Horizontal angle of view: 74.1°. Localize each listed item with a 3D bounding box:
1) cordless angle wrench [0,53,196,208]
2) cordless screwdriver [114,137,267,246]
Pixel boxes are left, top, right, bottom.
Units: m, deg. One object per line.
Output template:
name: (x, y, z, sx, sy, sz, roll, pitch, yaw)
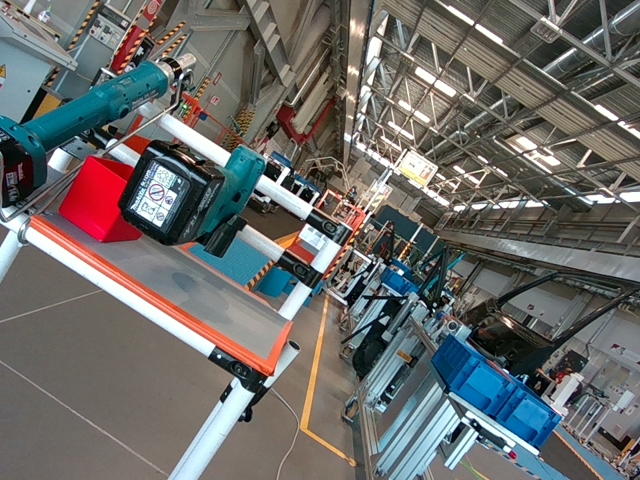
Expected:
cordless angle wrench: (-0.319, -0.205, 0.634, 0.074, 0.421, 0.098, 37, -44, -4)
cordless screwdriver: (-0.149, -0.044, 0.526, 0.074, 0.159, 0.248, 32, 13, 2)
